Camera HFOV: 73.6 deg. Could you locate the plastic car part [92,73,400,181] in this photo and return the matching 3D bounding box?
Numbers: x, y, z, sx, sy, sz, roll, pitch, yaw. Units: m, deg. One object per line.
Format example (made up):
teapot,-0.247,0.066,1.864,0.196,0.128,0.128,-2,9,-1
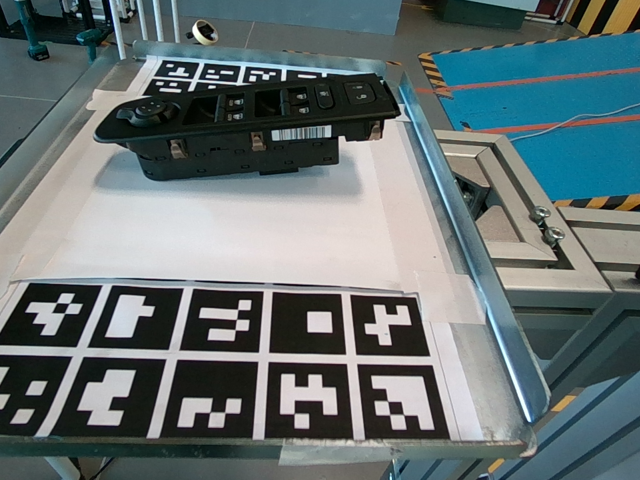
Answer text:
plastic car part,-0.052,-0.079,0.311,0.203,0.066,0.067,-3,-39,-5
